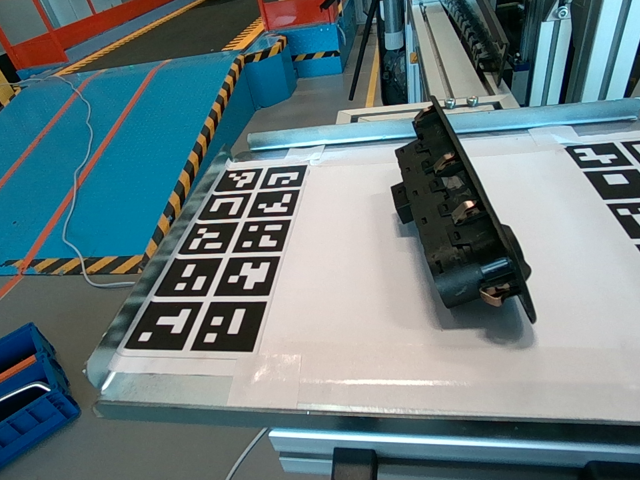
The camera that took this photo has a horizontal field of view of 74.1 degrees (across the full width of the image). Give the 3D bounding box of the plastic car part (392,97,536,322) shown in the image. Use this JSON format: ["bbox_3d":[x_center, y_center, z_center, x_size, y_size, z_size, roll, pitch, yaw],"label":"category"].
[{"bbox_3d":[0.088,-0.028,0.295,0.067,0.066,0.202,-19,37,11],"label":"plastic car part"}]
